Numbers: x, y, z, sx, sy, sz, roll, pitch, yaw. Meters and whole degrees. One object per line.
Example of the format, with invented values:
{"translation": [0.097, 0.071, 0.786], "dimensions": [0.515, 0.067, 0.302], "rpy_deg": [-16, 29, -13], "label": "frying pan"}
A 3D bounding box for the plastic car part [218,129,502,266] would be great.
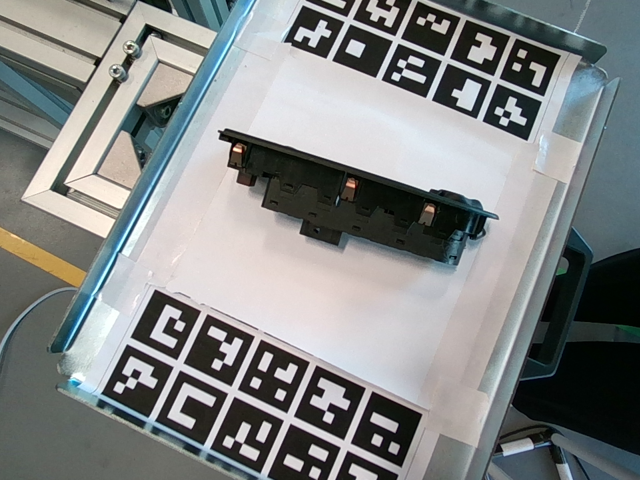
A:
{"translation": [0.026, -0.027, 0.303], "dimensions": [0.203, 0.067, 0.066], "rpy_deg": [14, 3, 4], "label": "plastic car part"}
